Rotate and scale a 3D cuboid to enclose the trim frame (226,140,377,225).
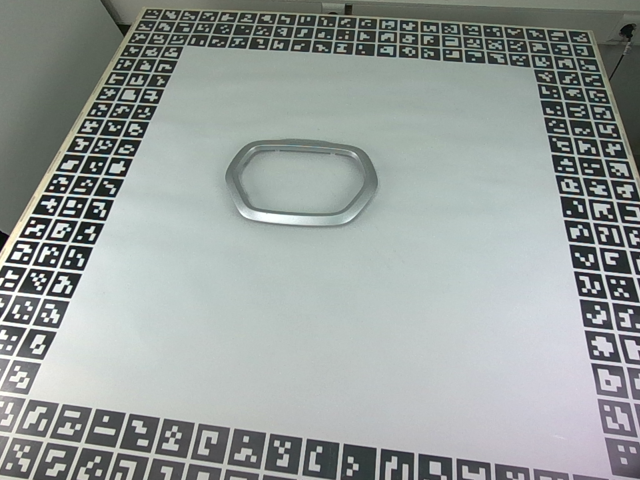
[{"bbox_3d":[-0.032,-0.101,0.694,0.249,0.183,0.027,2,-30,6],"label":"trim frame"}]
